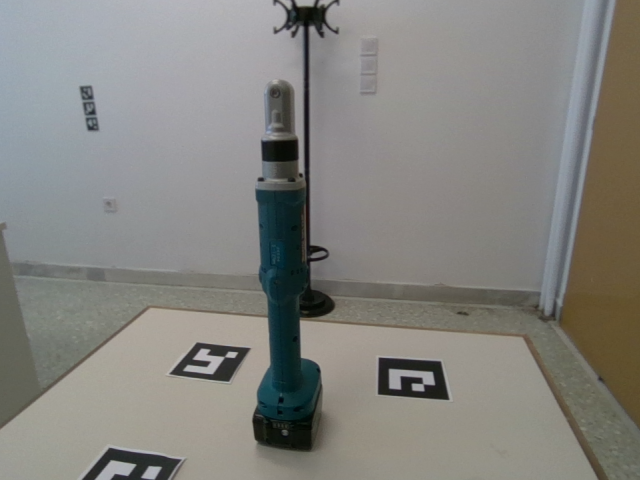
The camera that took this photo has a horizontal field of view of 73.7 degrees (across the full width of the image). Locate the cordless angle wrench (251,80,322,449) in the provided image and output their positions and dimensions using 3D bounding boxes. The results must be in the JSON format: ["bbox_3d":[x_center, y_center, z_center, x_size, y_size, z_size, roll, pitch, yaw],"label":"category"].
[{"bbox_3d":[-0.042,0.040,0.493,0.074,0.423,0.097,3,17,10],"label":"cordless angle wrench"}]
